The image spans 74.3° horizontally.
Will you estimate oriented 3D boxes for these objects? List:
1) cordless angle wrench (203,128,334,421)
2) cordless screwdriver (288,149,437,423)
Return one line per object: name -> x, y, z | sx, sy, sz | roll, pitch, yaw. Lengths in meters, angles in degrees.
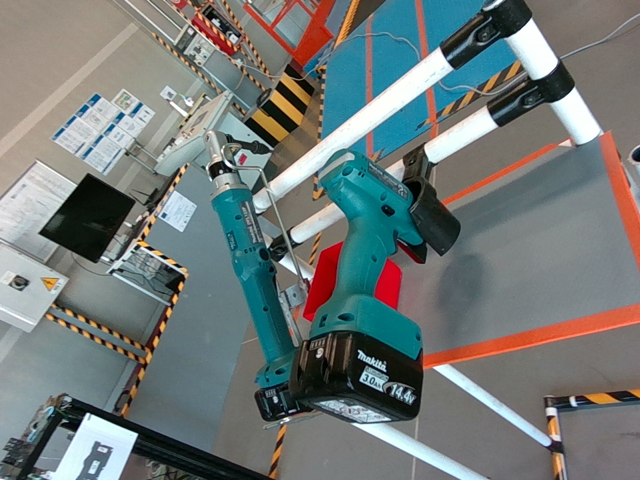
cordless angle wrench -> -0.095, 0.031, 0.601 | 0.074, 0.422, 0.098 | -25, -10, 33
cordless screwdriver -> 0.061, 0.042, 0.408 | 0.159, 0.248, 0.074 | 28, -36, -29
